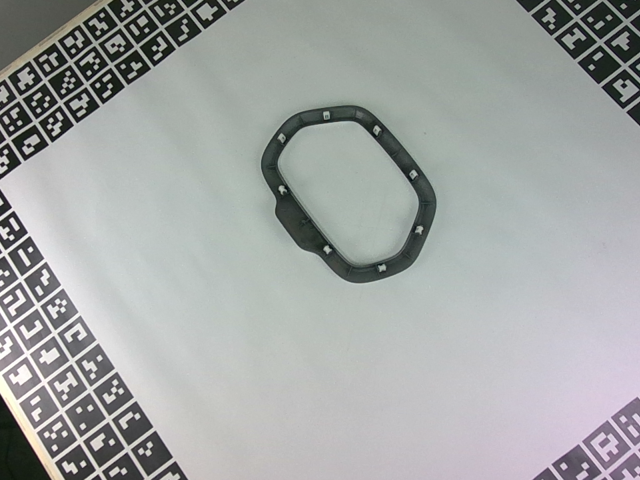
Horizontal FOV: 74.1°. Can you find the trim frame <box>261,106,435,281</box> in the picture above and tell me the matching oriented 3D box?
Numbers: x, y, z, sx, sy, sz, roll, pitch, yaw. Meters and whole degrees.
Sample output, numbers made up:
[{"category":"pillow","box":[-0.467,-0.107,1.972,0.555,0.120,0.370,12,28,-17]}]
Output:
[{"category":"trim frame","box":[0.033,-0.066,0.541,0.184,0.248,0.027,-36,-9,-2]}]
